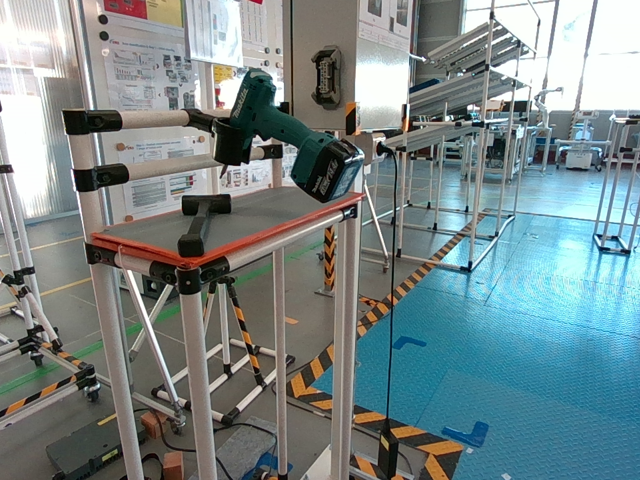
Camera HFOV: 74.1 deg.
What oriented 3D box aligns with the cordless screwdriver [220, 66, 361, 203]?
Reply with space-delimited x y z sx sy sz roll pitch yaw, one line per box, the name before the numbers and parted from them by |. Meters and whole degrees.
cordless screwdriver | -0.065 -0.152 0.702 0.249 0.160 0.074 42 33 15
